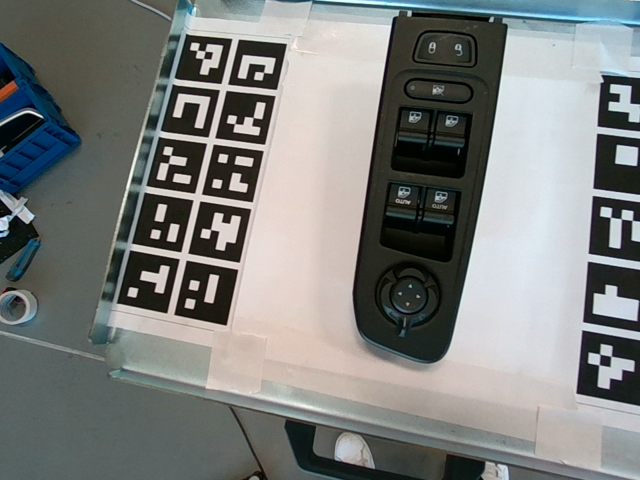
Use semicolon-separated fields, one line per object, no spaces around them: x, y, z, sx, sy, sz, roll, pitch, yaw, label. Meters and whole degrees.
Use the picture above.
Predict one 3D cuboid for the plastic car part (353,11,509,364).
0.061;-0.030;0.266;0.066;0.202;0.067;9;-6;0;plastic car part
